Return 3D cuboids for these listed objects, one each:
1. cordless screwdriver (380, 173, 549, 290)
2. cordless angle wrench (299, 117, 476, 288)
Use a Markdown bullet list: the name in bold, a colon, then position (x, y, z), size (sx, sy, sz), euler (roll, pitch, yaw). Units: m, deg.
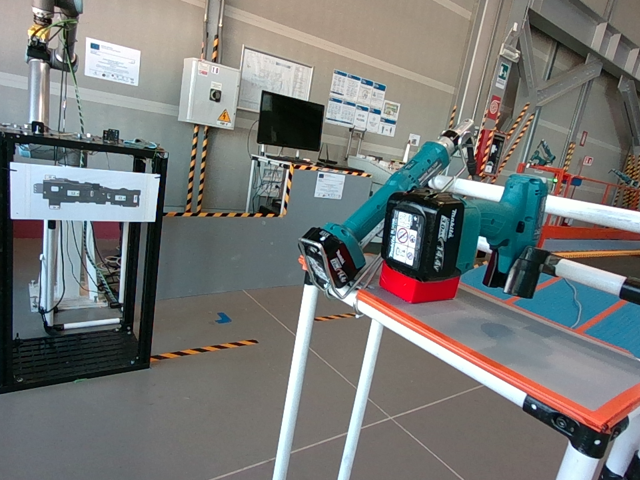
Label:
- **cordless screwdriver**: position (0.188, 0.004, 0.519), size (0.248, 0.159, 0.074), euler (-10, 19, -34)
- **cordless angle wrench**: position (0.144, -0.092, 0.751), size (0.422, 0.098, 0.074), euler (-43, 44, -17)
